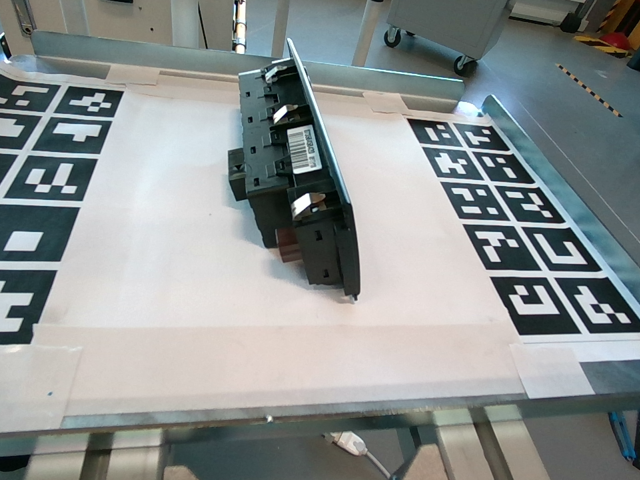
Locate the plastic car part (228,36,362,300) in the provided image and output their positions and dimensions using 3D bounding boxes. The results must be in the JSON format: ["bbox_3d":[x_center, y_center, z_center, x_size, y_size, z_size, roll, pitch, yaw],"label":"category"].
[{"bbox_3d":[-0.021,-0.056,0.263,0.067,0.202,0.066,-15,-43,7],"label":"plastic car part"}]
